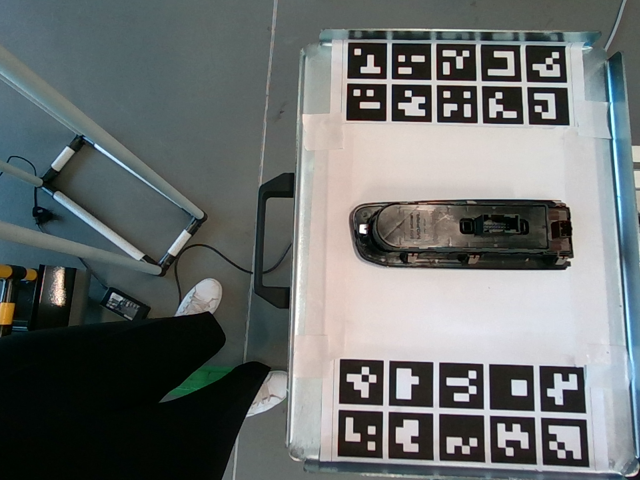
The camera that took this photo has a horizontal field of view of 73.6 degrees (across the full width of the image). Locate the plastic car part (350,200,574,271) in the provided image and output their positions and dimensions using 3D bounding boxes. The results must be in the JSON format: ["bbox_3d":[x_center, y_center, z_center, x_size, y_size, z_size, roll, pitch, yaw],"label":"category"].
[{"bbox_3d":[0.128,-0.006,0.376,0.203,0.066,0.067,0,-2,3],"label":"plastic car part"}]
